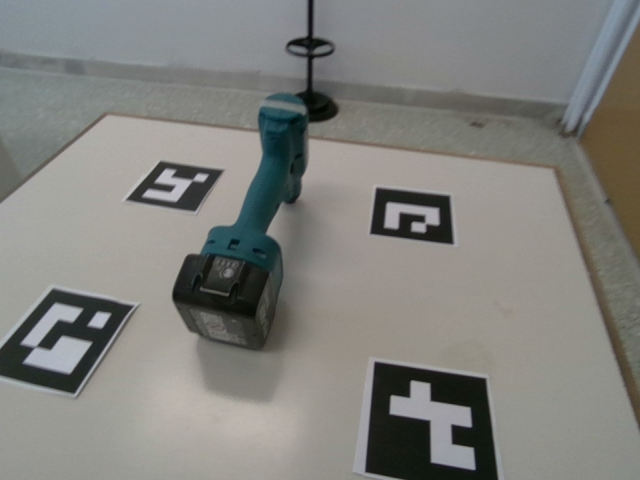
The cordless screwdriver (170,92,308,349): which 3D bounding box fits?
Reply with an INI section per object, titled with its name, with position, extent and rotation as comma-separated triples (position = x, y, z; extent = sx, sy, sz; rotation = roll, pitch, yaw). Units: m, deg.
[cordless screwdriver]
position = -0.062, -0.013, 0.447
extent = 0.074, 0.248, 0.159
rotation = 11, -30, 5
